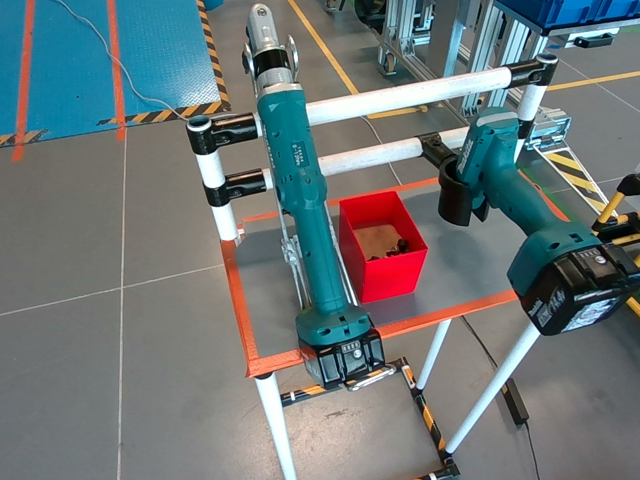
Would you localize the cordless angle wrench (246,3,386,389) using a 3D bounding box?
[{"bbox_3d":[-0.021,-0.055,0.475,0.074,0.423,0.098,-14,1,-17],"label":"cordless angle wrench"}]

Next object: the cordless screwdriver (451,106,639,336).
[{"bbox_3d":[0.224,-0.014,0.484,0.074,0.248,0.159,-13,-32,-8],"label":"cordless screwdriver"}]
